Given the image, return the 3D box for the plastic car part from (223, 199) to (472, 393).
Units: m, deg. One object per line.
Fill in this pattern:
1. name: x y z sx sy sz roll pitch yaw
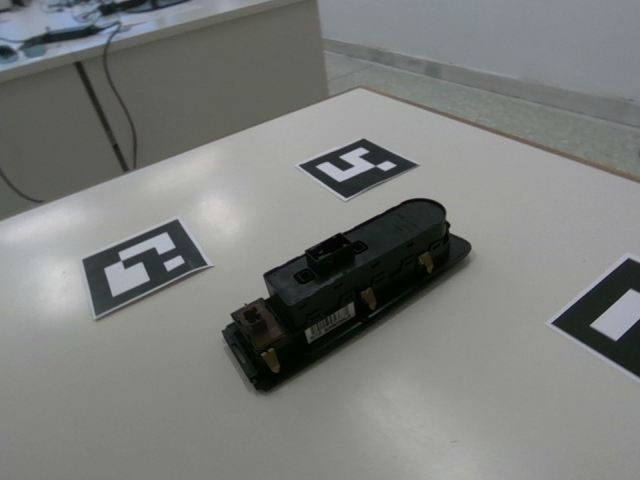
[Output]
1. plastic car part: 0.025 0.023 0.317 0.201 0.067 0.067 -24 31 -23
